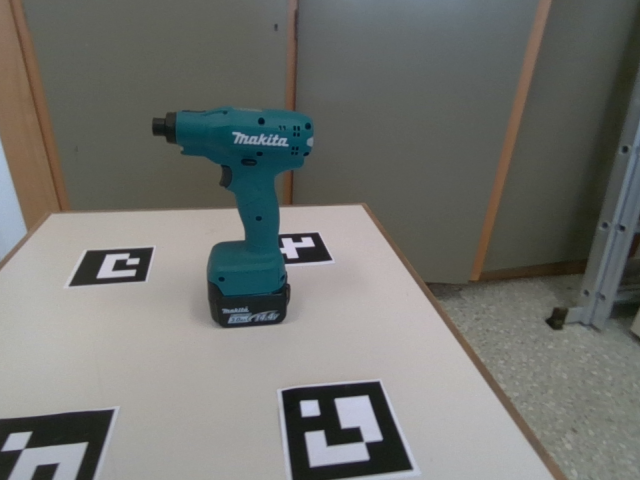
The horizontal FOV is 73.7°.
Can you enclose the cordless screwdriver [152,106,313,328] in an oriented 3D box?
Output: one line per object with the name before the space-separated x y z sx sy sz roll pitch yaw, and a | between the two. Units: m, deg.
cordless screwdriver | -0.099 -0.022 0.481 0.158 0.249 0.074 2 26 -10
